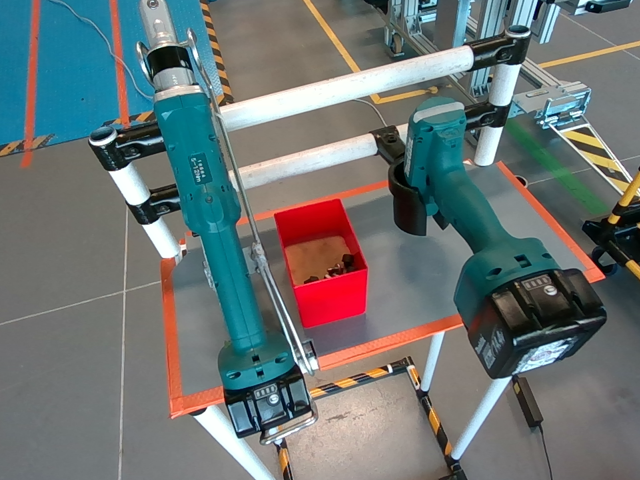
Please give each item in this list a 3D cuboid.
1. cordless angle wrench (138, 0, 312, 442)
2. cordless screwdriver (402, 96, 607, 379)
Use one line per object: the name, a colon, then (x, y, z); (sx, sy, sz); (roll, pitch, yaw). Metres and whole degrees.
cordless angle wrench: (-0.105, -0.030, 0.410); (0.074, 0.423, 0.098); (-16, 1, -12)
cordless screwdriver: (0.141, 0.002, 0.405); (0.074, 0.248, 0.159); (-15, -31, -5)
